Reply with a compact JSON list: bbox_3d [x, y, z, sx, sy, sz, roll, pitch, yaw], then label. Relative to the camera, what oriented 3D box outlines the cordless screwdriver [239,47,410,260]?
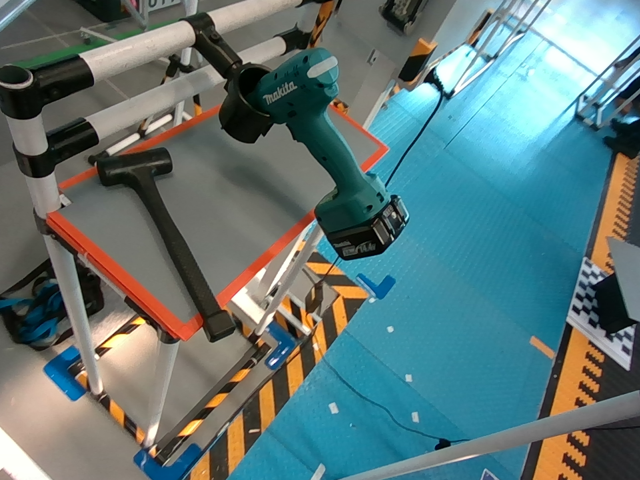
[{"bbox_3d":[-0.001,-0.094,0.530,0.159,0.249,0.074,-7,30,47],"label":"cordless screwdriver"}]
